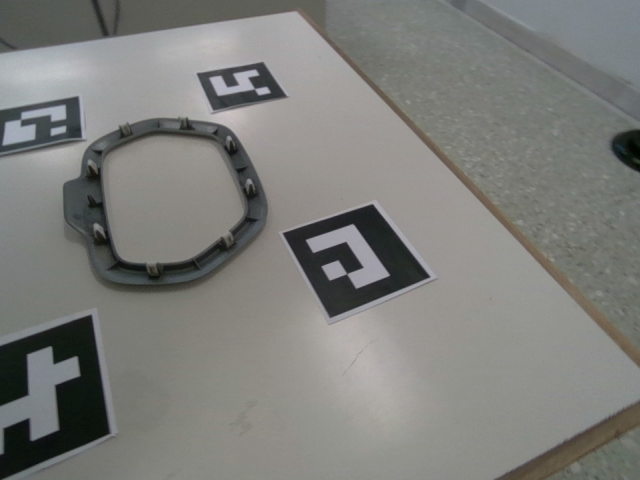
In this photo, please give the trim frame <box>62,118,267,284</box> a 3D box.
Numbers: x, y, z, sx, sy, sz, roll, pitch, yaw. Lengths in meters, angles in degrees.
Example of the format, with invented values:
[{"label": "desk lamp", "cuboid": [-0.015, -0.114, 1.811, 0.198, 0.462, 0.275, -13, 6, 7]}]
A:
[{"label": "trim frame", "cuboid": [-0.157, -0.056, 0.430, 0.183, 0.250, 0.027, -17, -37, -14]}]
